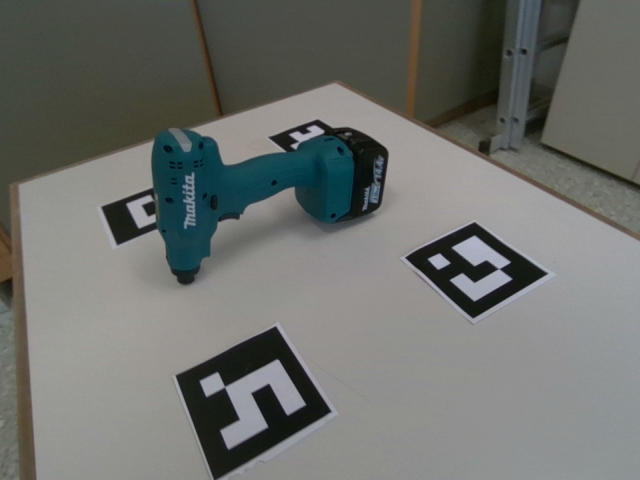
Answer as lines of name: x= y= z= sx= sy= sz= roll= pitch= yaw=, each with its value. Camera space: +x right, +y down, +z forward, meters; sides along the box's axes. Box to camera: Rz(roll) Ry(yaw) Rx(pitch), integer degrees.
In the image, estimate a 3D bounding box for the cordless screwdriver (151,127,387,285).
cordless screwdriver: x=-0.050 y=-0.042 z=0.466 sx=0.246 sy=0.159 sz=0.075 roll=-11 pitch=34 yaw=-29
